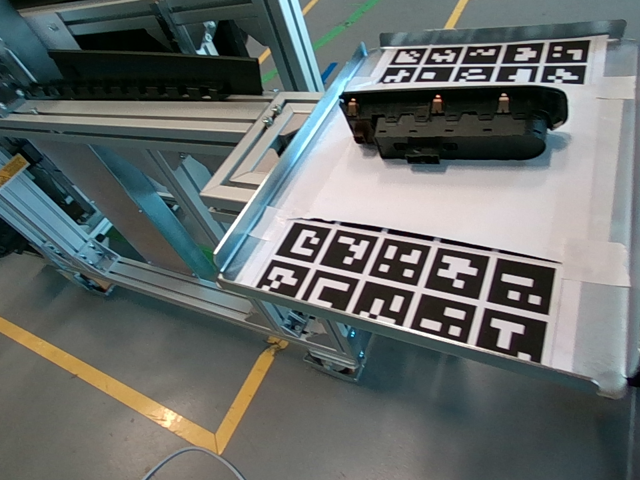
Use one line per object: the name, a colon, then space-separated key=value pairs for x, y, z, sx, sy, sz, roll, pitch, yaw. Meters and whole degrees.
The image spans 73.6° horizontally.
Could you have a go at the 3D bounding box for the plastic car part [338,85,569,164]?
plastic car part: x=0.116 y=-0.104 z=0.395 sx=0.204 sy=0.067 sz=0.066 roll=1 pitch=-29 yaw=22
